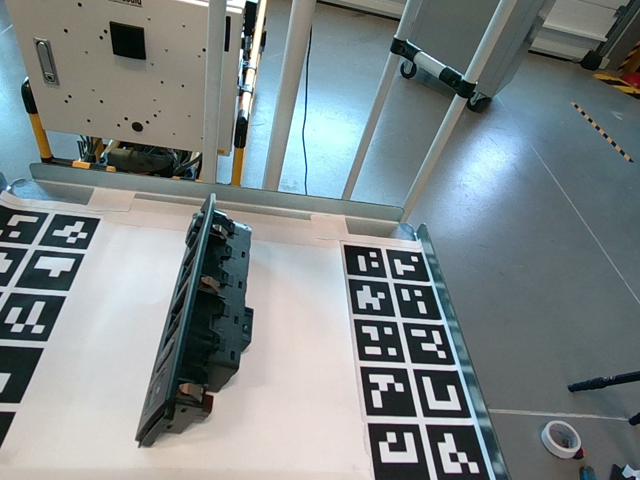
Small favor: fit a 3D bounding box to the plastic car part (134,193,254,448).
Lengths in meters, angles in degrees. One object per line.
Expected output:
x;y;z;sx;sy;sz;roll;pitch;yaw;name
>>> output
-0.082;0.043;0.323;0.067;0.202;0.067;14;-47;-21;plastic car part
